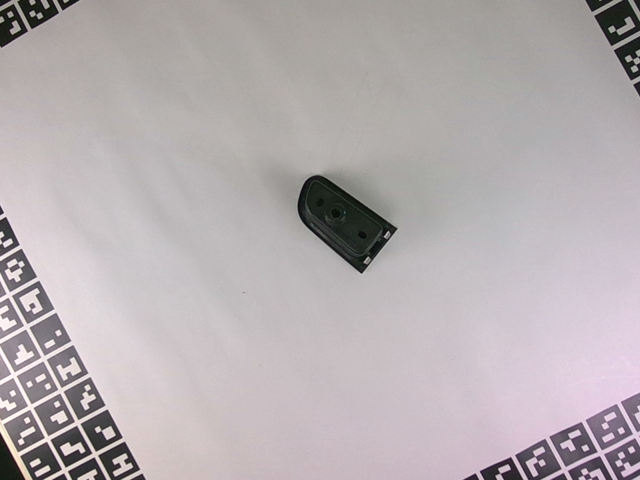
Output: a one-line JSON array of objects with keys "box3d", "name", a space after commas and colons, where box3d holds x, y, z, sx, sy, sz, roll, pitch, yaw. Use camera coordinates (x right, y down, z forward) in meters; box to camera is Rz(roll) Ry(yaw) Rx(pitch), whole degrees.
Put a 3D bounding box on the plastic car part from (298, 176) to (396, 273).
[{"box3d": [0.022, -0.022, 0.463, 0.116, 0.066, 0.071, 38, 1, -1], "name": "plastic car part"}]
